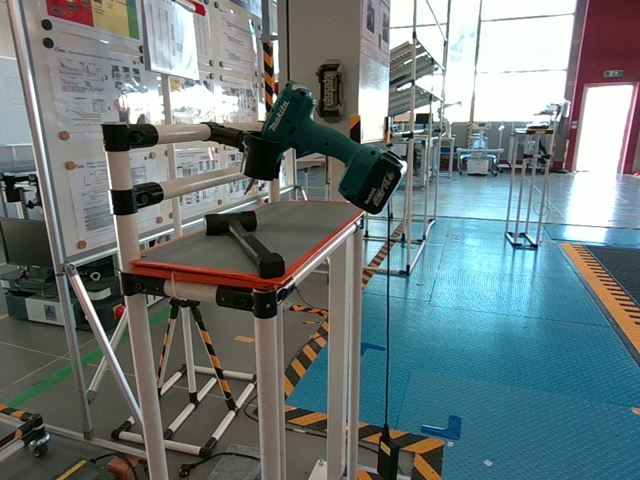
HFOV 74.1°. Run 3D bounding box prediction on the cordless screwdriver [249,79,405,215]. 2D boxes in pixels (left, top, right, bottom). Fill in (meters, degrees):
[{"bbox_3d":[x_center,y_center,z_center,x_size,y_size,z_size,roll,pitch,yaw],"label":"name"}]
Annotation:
[{"bbox_3d":[0.002,-0.129,0.696,0.249,0.160,0.074,36,24,7],"label":"cordless screwdriver"}]
